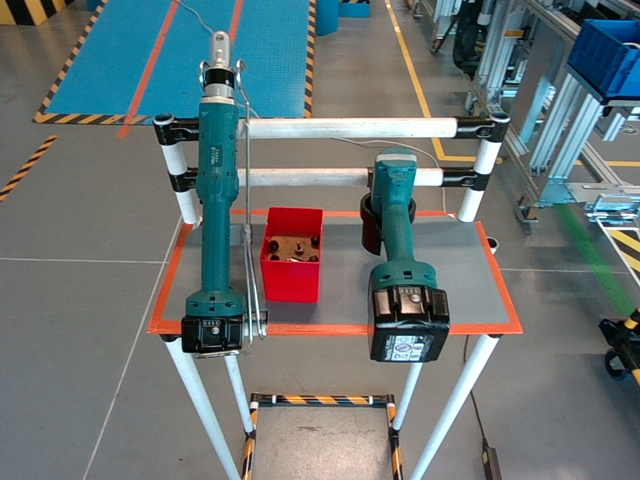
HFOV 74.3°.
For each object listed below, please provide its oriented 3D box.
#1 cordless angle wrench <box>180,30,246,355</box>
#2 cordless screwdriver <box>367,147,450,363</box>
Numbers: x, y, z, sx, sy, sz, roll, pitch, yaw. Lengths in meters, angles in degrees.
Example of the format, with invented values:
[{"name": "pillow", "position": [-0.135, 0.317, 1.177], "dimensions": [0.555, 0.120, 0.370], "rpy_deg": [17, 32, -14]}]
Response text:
[{"name": "cordless angle wrench", "position": [-0.135, -0.069, 0.557], "dimensions": [0.074, 0.422, 0.098], "rpy_deg": [1, -4, -7]}, {"name": "cordless screwdriver", "position": [0.092, 0.026, 0.514], "dimensions": [0.074, 0.248, 0.160], "rpy_deg": [1, -37, 3]}]
